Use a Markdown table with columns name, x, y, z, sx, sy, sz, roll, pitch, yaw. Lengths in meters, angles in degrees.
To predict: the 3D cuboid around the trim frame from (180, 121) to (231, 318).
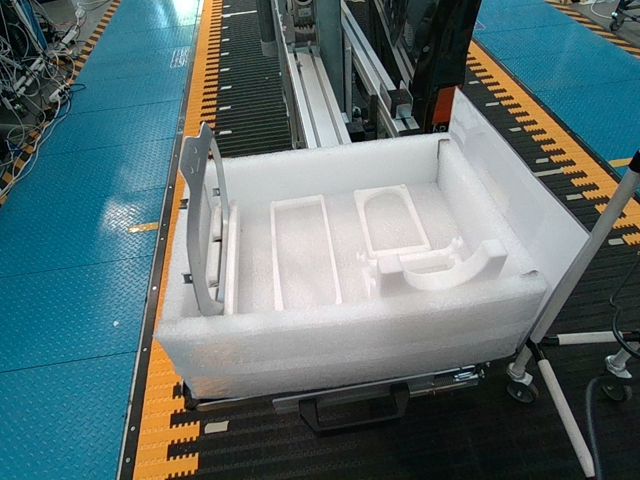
| name | x | y | z | sx | sy | sz | roll | pitch | yaw |
| --- | --- | --- | --- | --- | --- | --- | --- | --- | --- |
| trim frame | -0.128 | -0.026 | 0.489 | 0.027 | 0.248 | 0.184 | -3 | -42 | -3 |
